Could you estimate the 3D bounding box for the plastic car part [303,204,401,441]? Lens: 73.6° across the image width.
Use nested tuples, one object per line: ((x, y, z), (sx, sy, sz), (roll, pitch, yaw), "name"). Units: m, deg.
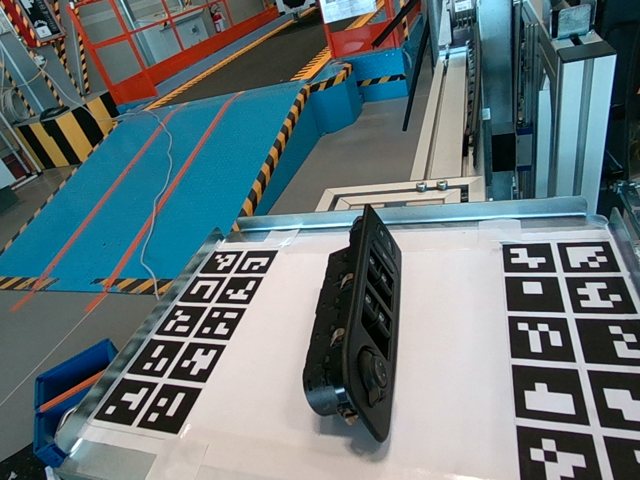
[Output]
((0.026, 0.052, 0.332), (0.067, 0.066, 0.202), (-18, 29, 18), "plastic car part")
